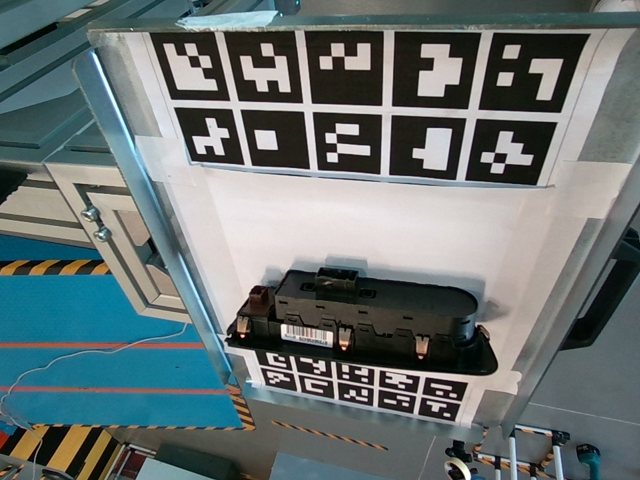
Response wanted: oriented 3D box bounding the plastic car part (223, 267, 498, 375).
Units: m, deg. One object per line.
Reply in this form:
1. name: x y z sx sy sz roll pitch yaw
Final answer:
1. plastic car part: 0.030 0.056 0.328 0.203 0.067 0.066 8 18 12
